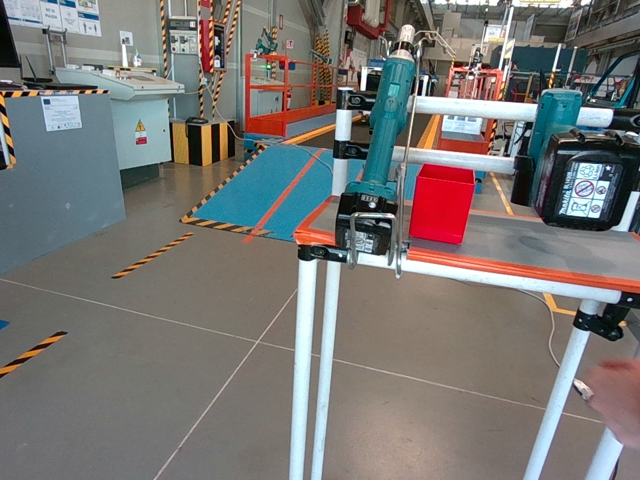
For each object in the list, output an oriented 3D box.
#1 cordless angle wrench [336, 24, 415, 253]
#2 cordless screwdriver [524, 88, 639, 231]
[{"bbox_3d":[0.105,-0.187,0.656,0.074,0.421,0.098,12,-24,7],"label":"cordless angle wrench"},{"bbox_3d":[0.292,-0.083,0.516,0.074,0.159,0.248,9,31,15],"label":"cordless screwdriver"}]
